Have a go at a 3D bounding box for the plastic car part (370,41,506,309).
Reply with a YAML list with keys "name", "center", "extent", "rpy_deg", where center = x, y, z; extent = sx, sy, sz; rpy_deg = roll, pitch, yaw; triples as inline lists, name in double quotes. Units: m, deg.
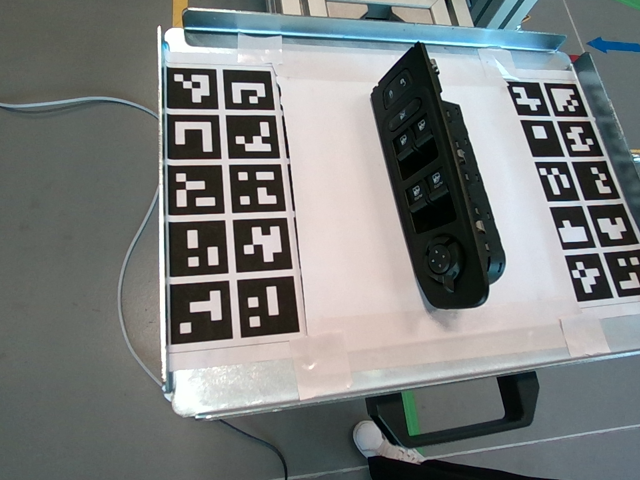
- name: "plastic car part"
  center: [0.093, -0.044, 0.332]
  extent: [0.067, 0.203, 0.067]
  rpy_deg: [10, -26, -38]
